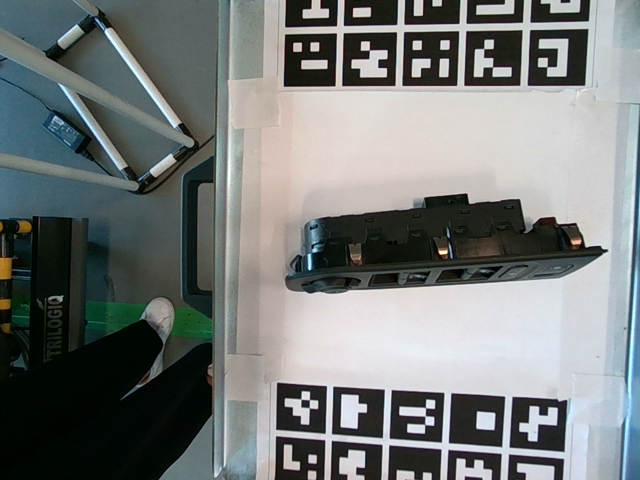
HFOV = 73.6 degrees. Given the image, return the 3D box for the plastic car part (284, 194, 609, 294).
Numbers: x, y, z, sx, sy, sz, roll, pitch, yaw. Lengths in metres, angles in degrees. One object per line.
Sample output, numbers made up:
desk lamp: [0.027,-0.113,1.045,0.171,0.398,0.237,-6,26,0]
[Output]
plastic car part: [0.072,0.004,0.293,0.203,0.067,0.066,-8,-11,2]
